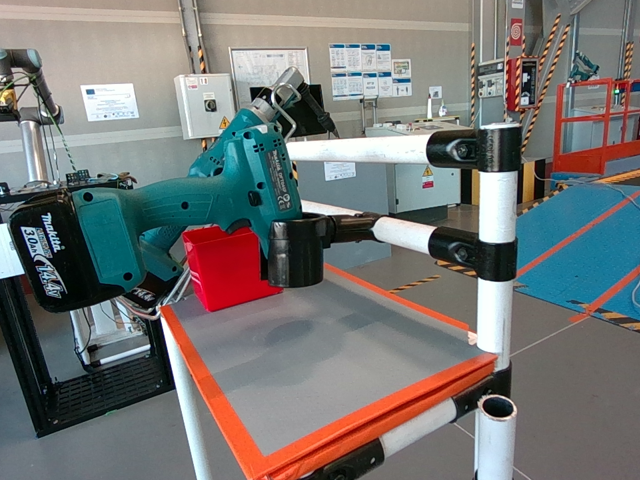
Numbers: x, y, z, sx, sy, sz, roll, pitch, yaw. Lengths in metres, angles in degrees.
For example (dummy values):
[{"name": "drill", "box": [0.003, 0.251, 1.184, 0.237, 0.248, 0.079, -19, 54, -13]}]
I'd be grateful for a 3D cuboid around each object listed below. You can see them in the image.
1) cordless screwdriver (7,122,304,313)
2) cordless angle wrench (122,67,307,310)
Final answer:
[{"name": "cordless screwdriver", "box": [-0.130, -0.004, 0.401, 0.248, 0.159, 0.074, -23, 21, -23]}, {"name": "cordless angle wrench", "box": [-0.156, -0.097, 0.626, 0.098, 0.422, 0.074, 43, -12, -36]}]
